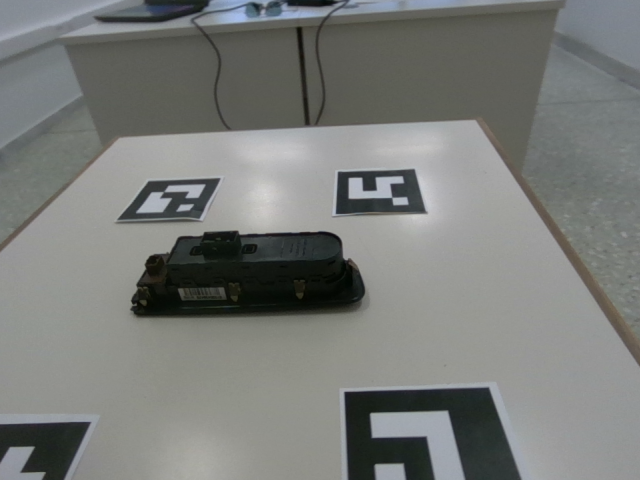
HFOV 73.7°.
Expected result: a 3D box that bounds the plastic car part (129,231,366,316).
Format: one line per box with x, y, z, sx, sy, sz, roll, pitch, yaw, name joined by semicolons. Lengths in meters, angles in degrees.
-0.063;0.023;0.370;0.203;0.067;0.066;1;27;5;plastic car part
